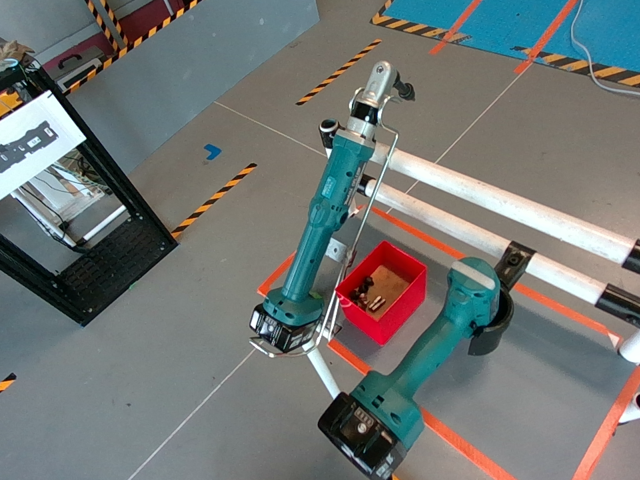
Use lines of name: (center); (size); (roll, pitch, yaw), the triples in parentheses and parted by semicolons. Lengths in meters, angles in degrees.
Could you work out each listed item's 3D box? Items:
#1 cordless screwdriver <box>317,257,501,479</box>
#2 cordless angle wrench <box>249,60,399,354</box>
cordless screwdriver: (0.116, 0.146, 0.475); (0.074, 0.248, 0.159); (34, -13, 34)
cordless angle wrench: (0.014, -0.040, 0.600); (0.074, 0.423, 0.098); (29, 16, 28)
